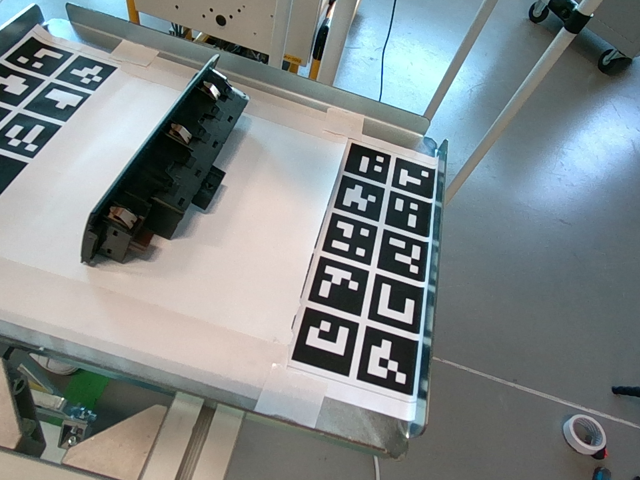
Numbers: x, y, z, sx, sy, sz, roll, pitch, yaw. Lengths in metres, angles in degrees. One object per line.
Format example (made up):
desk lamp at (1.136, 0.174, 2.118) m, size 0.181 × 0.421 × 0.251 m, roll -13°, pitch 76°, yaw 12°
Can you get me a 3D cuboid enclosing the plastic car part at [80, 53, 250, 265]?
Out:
plastic car part at (-0.102, -0.067, 0.324) m, size 0.067 × 0.202 × 0.067 m, roll 22°, pitch -35°, yaw -14°
